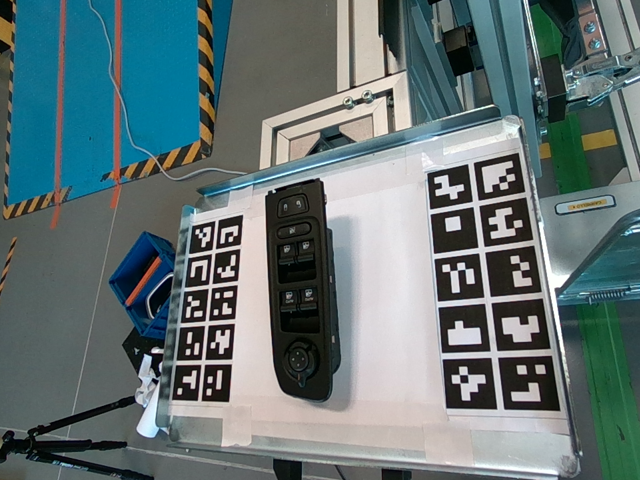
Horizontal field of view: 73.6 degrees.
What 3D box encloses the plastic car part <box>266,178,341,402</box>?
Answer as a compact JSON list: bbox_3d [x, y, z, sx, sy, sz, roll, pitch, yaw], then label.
[{"bbox_3d":[-0.013,0.048,0.415,0.067,0.202,0.067,-8,-18,20],"label":"plastic car part"}]
